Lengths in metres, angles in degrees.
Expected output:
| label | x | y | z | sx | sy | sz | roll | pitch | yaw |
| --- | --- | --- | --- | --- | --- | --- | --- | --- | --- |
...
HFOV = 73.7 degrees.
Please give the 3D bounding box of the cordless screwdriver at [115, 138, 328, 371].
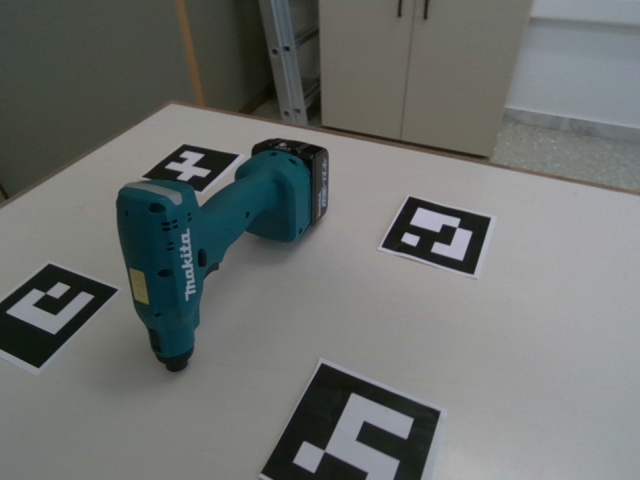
| label | x | y | z | sx | sy | sz | roll | pitch | yaw |
| --- | --- | --- | --- | --- | --- | --- | --- | --- | --- |
| cordless screwdriver | -0.076 | -0.003 | 0.407 | 0.075 | 0.159 | 0.247 | 13 | 28 | 23 |
